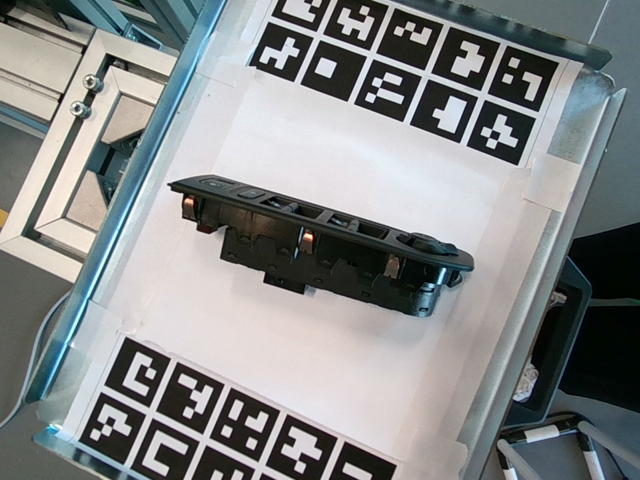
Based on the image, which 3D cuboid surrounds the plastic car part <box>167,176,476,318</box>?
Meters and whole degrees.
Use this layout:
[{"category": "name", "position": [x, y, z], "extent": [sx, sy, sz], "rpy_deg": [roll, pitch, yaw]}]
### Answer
[{"category": "plastic car part", "position": [0.000, 0.006, 0.287], "extent": [0.203, 0.067, 0.066], "rpy_deg": [13, 5, 8]}]
